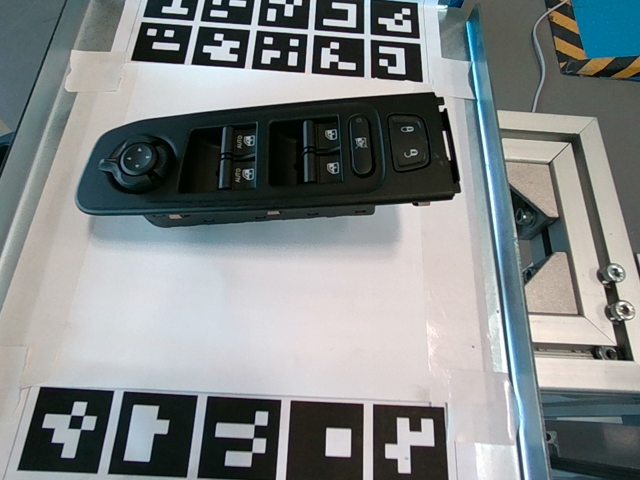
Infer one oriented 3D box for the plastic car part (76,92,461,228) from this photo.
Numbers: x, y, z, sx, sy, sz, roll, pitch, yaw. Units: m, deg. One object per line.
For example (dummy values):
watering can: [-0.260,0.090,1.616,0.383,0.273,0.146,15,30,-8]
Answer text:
plastic car part: [-0.032,-0.040,0.248,0.203,0.066,0.067,-2,-16,1]
